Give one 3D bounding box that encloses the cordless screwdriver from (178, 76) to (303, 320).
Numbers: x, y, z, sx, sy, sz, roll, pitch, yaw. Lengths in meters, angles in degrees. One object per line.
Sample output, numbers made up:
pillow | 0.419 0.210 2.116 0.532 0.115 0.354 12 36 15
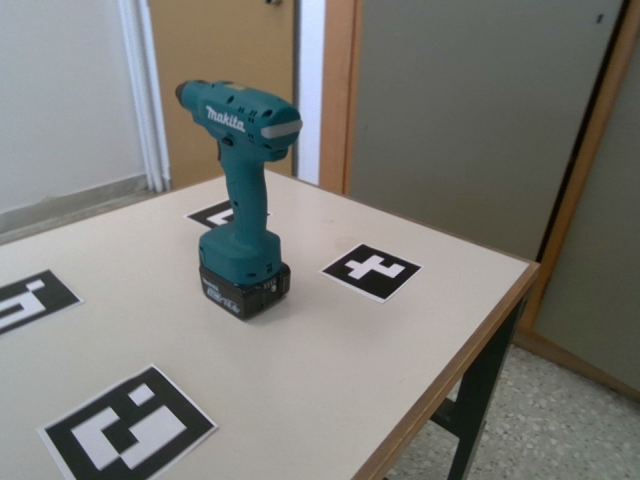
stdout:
cordless screwdriver | -0.098 -0.046 0.470 0.160 0.249 0.073 30 39 33
